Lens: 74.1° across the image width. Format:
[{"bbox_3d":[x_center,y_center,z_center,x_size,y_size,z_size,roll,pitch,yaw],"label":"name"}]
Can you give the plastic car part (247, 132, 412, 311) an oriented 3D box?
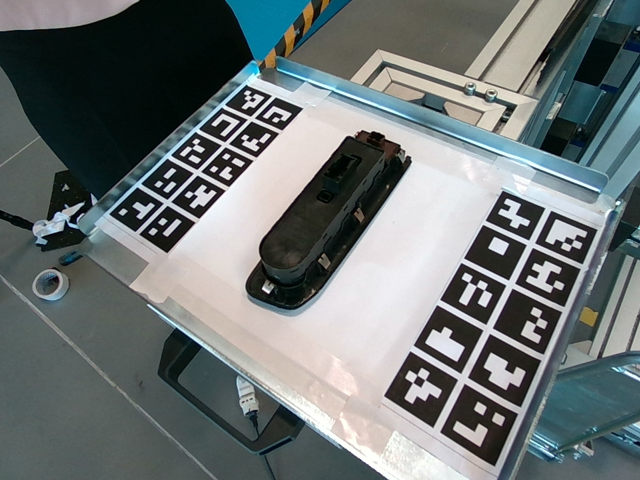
[{"bbox_3d":[0.011,-0.028,0.372,0.066,0.202,0.067,30,-21,15],"label":"plastic car part"}]
